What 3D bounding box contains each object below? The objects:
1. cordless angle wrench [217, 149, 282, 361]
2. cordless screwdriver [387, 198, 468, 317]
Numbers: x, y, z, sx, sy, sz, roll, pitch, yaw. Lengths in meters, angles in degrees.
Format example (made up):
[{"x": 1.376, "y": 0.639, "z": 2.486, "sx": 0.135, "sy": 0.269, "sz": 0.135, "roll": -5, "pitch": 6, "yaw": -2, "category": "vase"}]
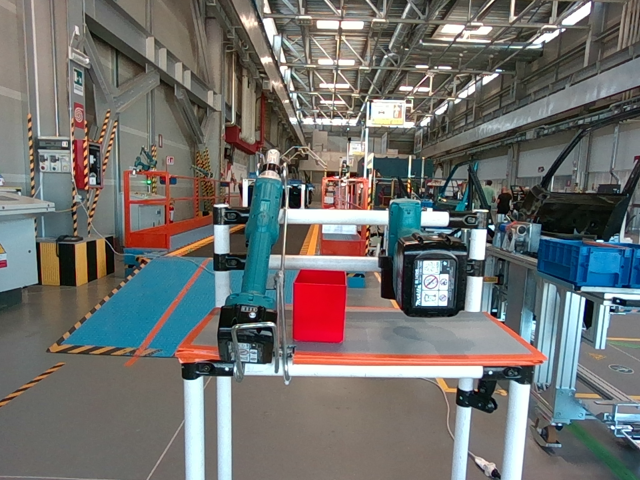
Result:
[{"x": -0.096, "y": -0.014, "z": 0.702, "sx": 0.074, "sy": 0.421, "sz": 0.098, "roll": 4, "pitch": -40, "yaw": -4, "category": "cordless angle wrench"}, {"x": 0.131, "y": 0.038, "z": 0.595, "sx": 0.074, "sy": 0.159, "sz": 0.248, "roll": 1, "pitch": 15, "yaw": 2, "category": "cordless screwdriver"}]
